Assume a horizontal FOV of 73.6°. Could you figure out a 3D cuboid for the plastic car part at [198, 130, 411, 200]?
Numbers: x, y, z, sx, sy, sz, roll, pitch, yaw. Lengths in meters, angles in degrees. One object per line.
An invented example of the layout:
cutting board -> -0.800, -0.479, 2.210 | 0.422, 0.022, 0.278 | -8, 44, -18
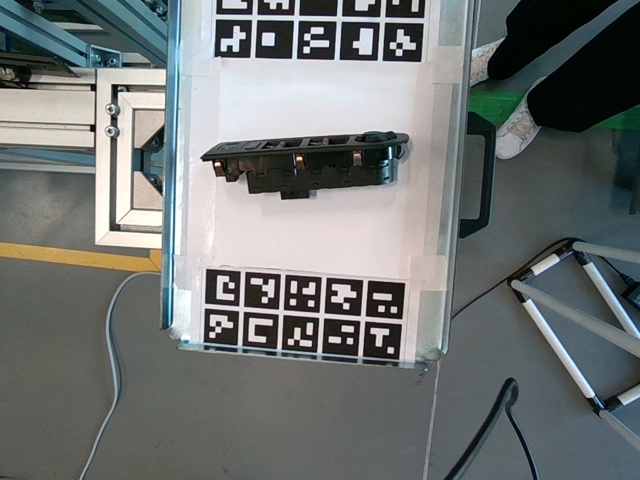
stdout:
plastic car part -> -0.011, -0.075, 0.425 | 0.203, 0.067, 0.066 | -6, 15, 10
